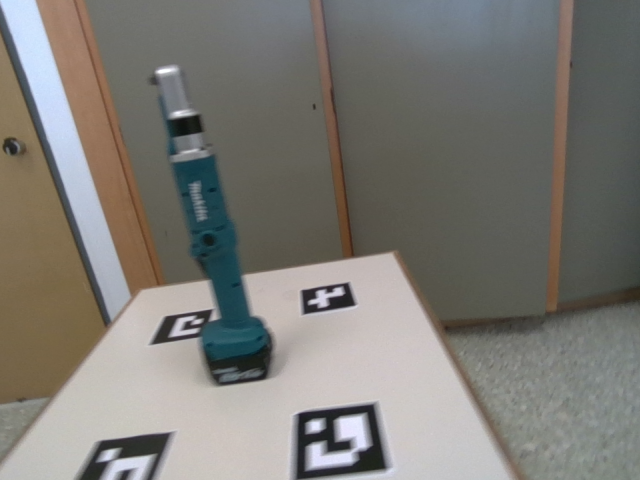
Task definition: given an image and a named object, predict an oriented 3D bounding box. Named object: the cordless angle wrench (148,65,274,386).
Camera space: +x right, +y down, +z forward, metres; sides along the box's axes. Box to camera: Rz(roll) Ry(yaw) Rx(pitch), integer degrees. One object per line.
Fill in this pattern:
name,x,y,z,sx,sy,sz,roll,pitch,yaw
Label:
cordless angle wrench,-0.144,-0.007,0.567,0.098,0.422,0.074,-9,18,1
